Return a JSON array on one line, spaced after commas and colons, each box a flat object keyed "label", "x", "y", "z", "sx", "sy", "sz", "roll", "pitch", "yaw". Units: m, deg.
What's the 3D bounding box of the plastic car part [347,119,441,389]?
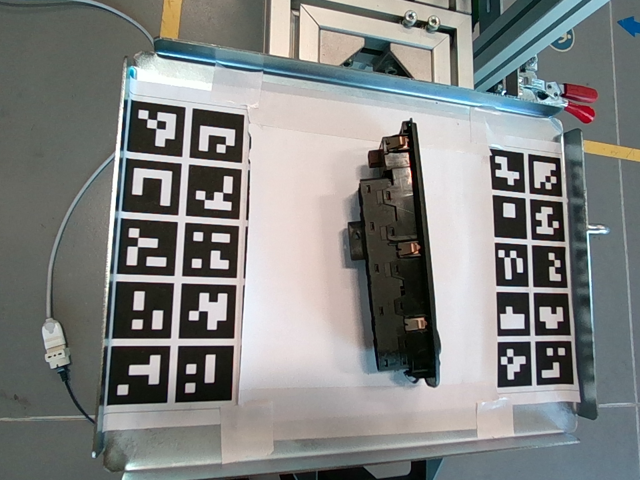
[{"label": "plastic car part", "x": 0.058, "y": 0.016, "z": 0.329, "sx": 0.067, "sy": 0.202, "sz": 0.066, "roll": -9, "pitch": -5, "yaw": -4}]
